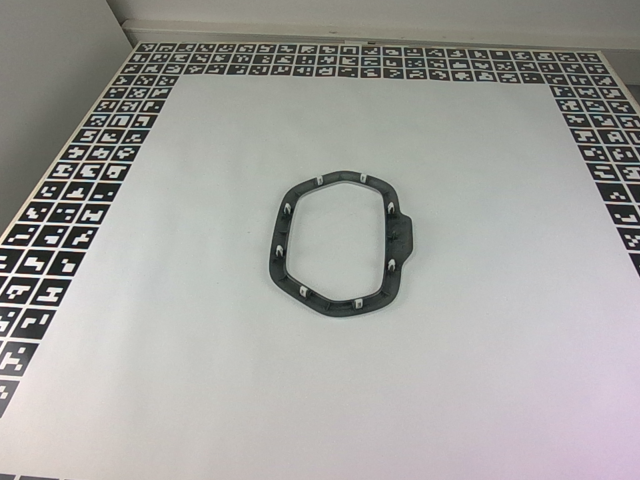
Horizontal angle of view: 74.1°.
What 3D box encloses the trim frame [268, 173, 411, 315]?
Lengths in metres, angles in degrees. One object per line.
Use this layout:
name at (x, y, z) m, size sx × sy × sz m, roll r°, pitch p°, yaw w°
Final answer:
trim frame at (0.027, -0.009, 0.569) m, size 0.184 × 0.247 × 0.027 m, roll 4°, pitch -42°, yaw 5°
